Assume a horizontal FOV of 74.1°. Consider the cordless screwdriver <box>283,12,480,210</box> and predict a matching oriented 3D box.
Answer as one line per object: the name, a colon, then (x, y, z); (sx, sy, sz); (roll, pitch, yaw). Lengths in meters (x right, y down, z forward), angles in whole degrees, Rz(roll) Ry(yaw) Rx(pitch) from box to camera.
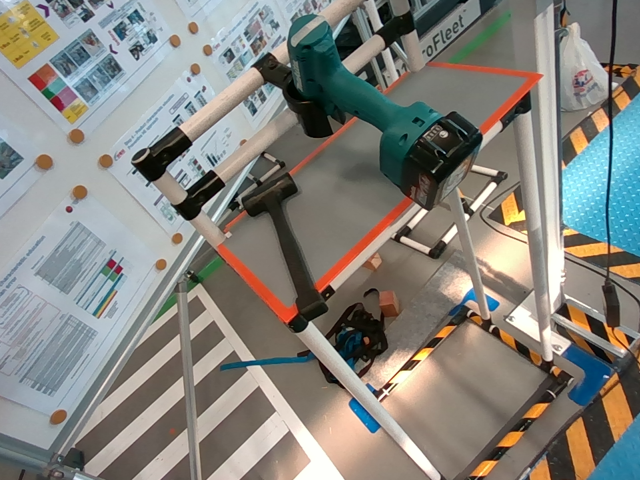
cordless screwdriver: (0.056, -0.139, 0.504); (0.249, 0.074, 0.159); (44, -11, 16)
